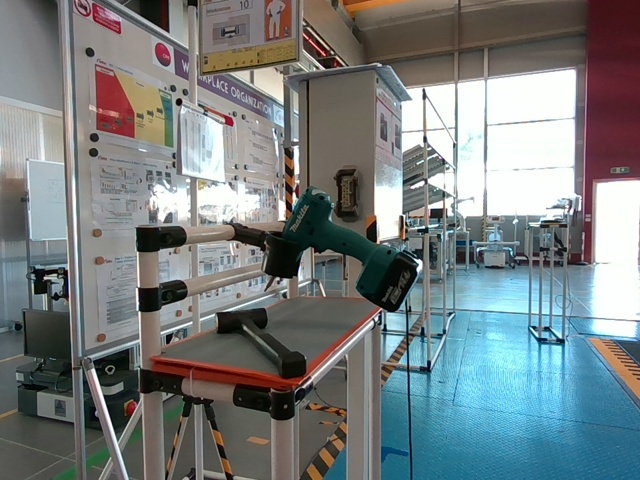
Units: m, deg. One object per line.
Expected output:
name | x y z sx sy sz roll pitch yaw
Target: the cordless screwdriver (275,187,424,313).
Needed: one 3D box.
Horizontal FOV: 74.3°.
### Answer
cordless screwdriver | 0.041 0.036 0.729 0.248 0.159 0.074 34 17 15
